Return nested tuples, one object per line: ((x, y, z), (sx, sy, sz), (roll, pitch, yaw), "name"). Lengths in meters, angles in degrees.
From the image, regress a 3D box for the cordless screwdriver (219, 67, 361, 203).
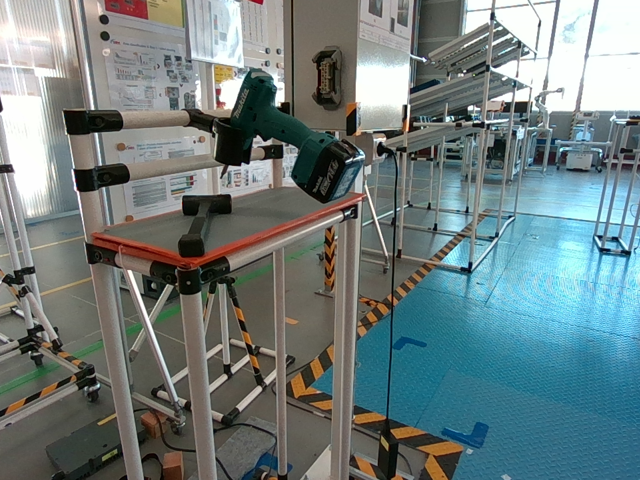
((-0.066, -0.153, 0.707), (0.249, 0.160, 0.074), (42, 32, 14), "cordless screwdriver")
